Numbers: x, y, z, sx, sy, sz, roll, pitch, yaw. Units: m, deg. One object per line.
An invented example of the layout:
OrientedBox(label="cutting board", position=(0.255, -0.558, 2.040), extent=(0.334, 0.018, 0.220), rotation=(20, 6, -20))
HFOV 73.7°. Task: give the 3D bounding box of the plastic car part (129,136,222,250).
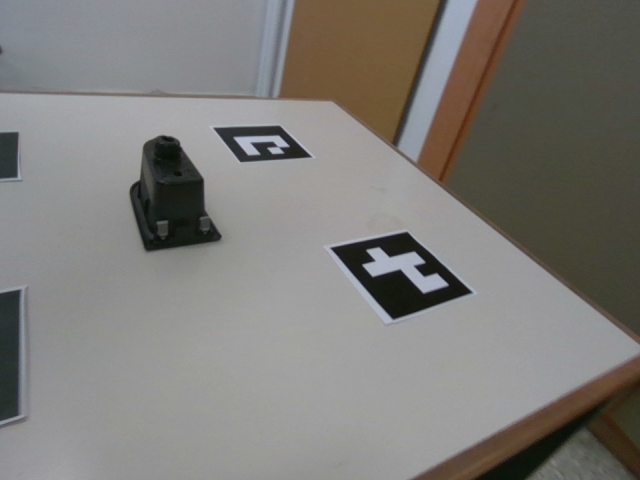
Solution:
OrientedBox(label="plastic car part", position=(-0.136, -0.054, 0.384), extent=(0.065, 0.071, 0.117), rotation=(-8, 44, -30))
